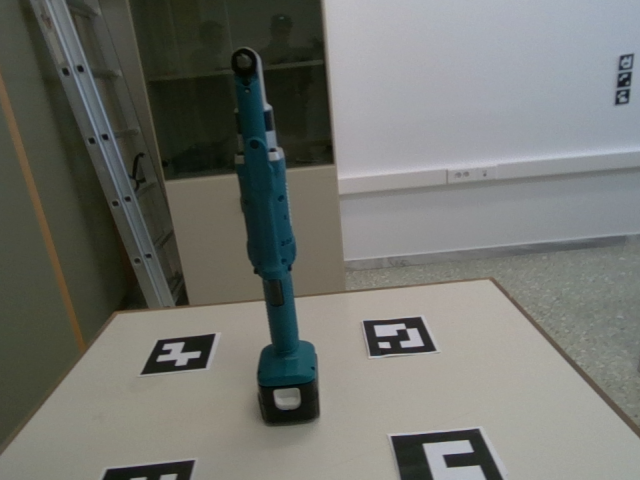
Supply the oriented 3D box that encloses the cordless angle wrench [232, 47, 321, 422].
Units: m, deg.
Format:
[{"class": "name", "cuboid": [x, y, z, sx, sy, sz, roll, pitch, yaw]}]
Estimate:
[{"class": "cordless angle wrench", "cuboid": [-0.053, 0.011, 0.488, 0.074, 0.422, 0.098, -5, 19, 0]}]
